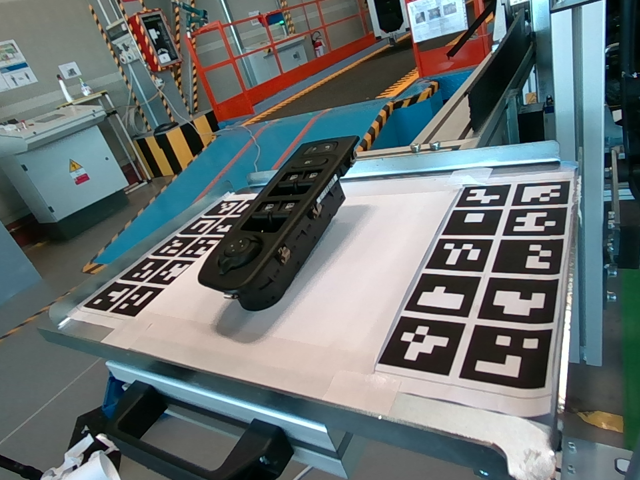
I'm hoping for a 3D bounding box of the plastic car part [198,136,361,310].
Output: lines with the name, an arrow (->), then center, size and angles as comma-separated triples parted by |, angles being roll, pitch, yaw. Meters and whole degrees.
plastic car part -> -0.027, -0.017, 0.365 | 0.067, 0.067, 0.202 | 8, 41, 28
